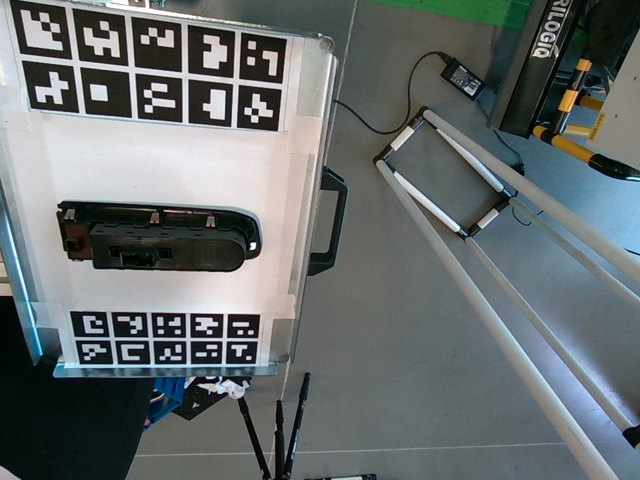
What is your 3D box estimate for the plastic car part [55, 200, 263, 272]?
[{"bbox_3d":[-0.158,0.001,0.431,0.202,0.066,0.067,0,24,-12],"label":"plastic car part"}]
